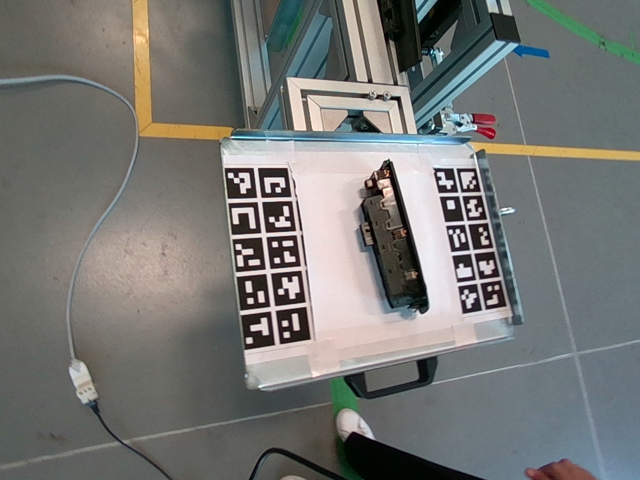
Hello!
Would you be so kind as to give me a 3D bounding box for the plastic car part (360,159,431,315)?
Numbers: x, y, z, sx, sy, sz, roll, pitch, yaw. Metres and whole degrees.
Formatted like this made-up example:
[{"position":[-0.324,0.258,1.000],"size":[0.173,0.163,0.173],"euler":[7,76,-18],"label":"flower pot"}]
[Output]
[{"position":[0.093,0.004,0.551],"size":[0.067,0.203,0.066],"euler":[-17,-5,-12],"label":"plastic car part"}]
